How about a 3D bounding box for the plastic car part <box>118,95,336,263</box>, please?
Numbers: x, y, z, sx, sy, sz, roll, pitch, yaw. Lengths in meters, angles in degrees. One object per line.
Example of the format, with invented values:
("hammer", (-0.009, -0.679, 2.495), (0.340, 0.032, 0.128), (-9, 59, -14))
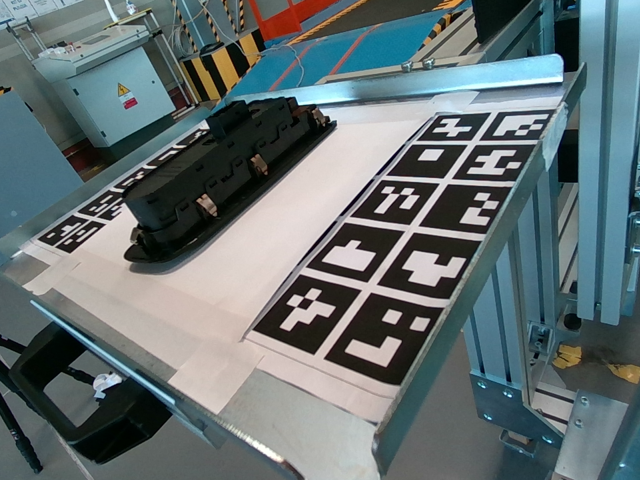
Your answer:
("plastic car part", (-0.069, -0.060, 0.321), (0.067, 0.067, 0.202), (14, 51, 34))
